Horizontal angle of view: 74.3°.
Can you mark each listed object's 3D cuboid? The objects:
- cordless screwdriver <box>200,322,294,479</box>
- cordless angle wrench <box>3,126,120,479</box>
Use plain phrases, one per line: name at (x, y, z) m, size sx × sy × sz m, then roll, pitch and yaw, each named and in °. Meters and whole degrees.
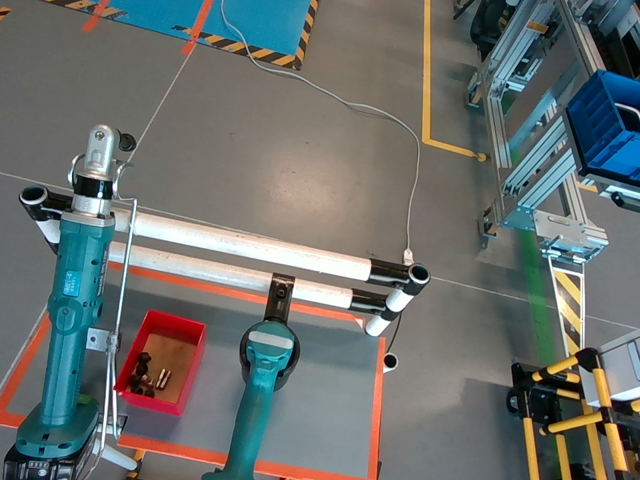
cordless screwdriver at (-0.084, 0.229, 0.485) m, size 0.074 × 0.248 × 0.159 m, roll 14°, pitch -27°, yaw -2°
cordless angle wrench at (-0.285, 0.078, 0.497) m, size 0.074 × 0.423 × 0.098 m, roll 11°, pitch 6°, yaw -10°
